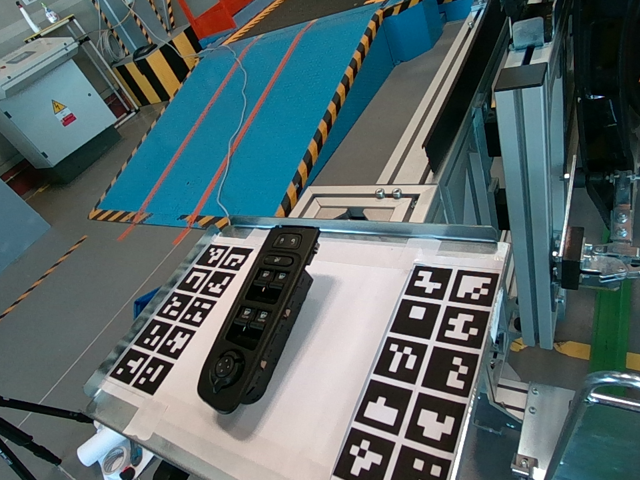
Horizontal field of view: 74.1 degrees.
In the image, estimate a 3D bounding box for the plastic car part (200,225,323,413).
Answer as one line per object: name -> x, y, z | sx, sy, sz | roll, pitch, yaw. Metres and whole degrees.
plastic car part -> -0.054, 0.079, 0.437 | 0.067, 0.202, 0.067 | 9, -35, 27
